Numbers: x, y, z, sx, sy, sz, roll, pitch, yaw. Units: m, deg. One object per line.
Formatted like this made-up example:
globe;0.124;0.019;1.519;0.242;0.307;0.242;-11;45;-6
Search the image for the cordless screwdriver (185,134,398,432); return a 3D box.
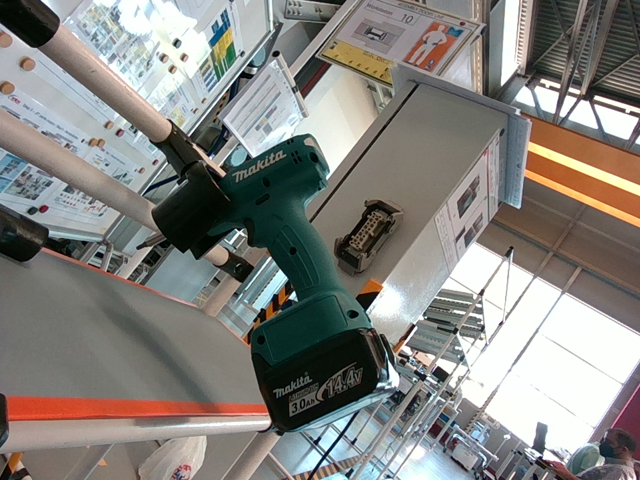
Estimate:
cordless screwdriver;-0.041;0.034;0.369;0.159;0.248;0.074;-25;-27;12
